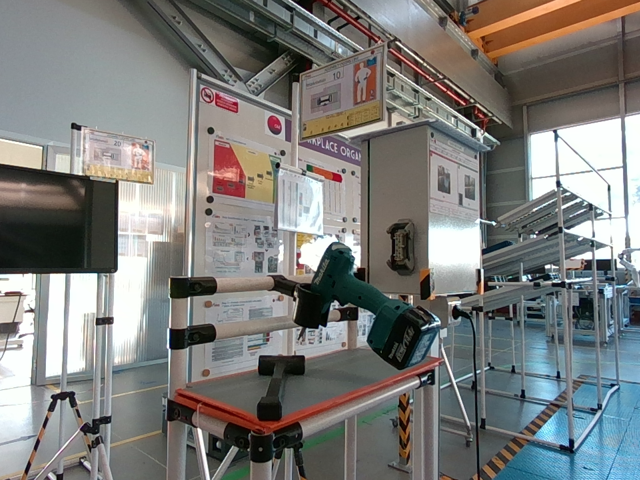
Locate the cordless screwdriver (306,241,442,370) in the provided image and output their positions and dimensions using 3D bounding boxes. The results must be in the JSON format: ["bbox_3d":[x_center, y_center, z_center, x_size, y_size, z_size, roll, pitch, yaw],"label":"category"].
[{"bbox_3d":[0.074,0.129,0.740,0.074,0.159,0.248,0,31,-49],"label":"cordless screwdriver"}]
